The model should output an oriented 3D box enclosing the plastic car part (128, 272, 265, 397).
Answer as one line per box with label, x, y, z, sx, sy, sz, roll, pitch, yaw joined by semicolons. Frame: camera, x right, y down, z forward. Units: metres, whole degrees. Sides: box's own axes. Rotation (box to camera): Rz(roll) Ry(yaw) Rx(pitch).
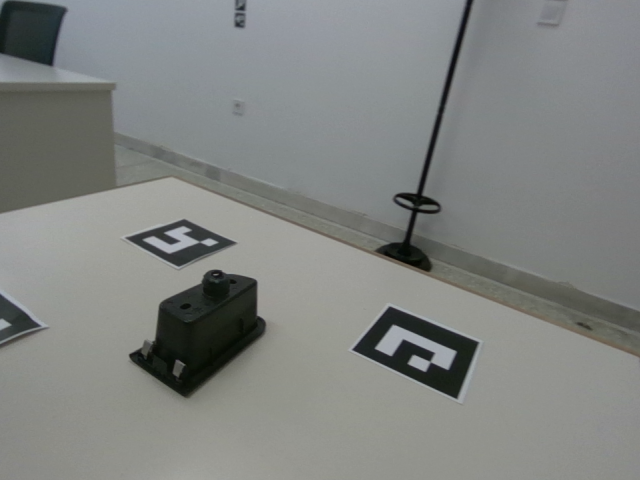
plastic car part;-0.096;0.064;0.368;0.066;0.071;0.115;22;31;24
